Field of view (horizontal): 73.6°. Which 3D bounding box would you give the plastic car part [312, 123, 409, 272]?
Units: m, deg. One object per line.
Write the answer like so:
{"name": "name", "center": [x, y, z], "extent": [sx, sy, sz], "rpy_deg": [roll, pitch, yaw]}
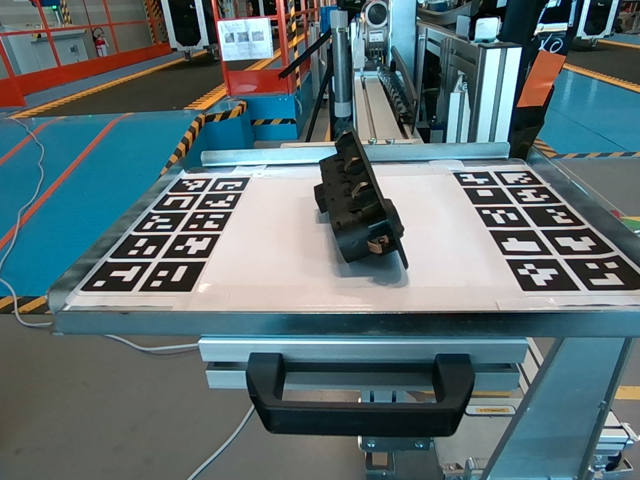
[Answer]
{"name": "plastic car part", "center": [0.028, -0.041, 0.372], "extent": [0.067, 0.066, 0.203], "rpy_deg": [-16, 30, 0]}
